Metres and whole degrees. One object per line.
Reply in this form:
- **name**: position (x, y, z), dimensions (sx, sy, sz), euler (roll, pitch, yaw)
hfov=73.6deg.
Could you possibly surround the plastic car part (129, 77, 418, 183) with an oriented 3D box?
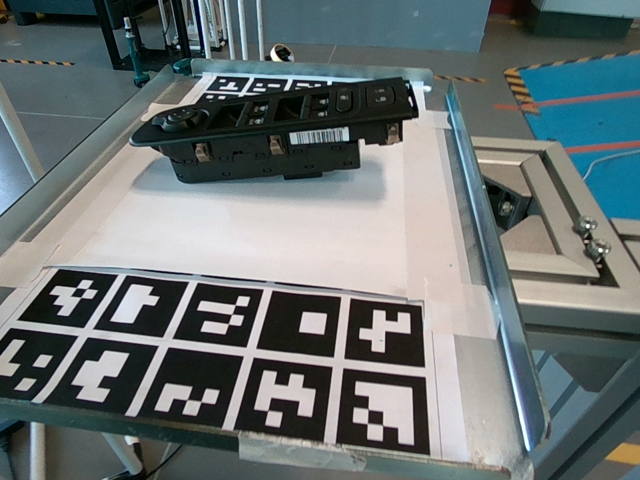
- **plastic car part**: position (-0.035, -0.078, 0.320), dimensions (0.203, 0.066, 0.067), euler (-1, -40, 6)
